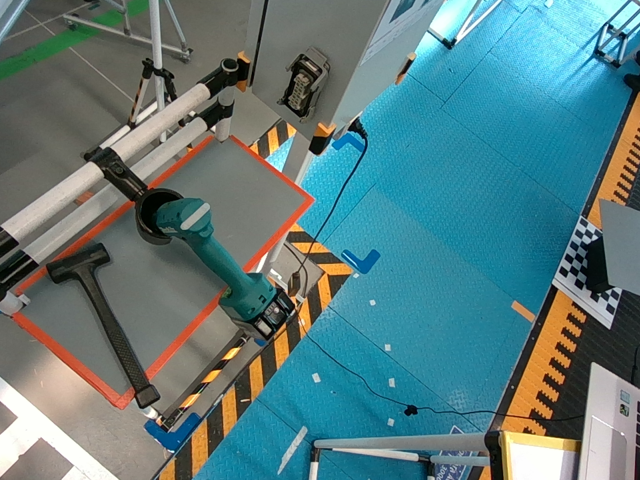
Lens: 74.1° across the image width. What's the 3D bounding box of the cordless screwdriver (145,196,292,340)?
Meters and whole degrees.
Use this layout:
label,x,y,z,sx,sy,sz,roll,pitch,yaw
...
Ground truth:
label,x,y,z,sx,sy,sz,roll,pitch,yaw
cordless screwdriver,-0.163,0.040,0.646,0.160,0.248,0.074,2,44,51
